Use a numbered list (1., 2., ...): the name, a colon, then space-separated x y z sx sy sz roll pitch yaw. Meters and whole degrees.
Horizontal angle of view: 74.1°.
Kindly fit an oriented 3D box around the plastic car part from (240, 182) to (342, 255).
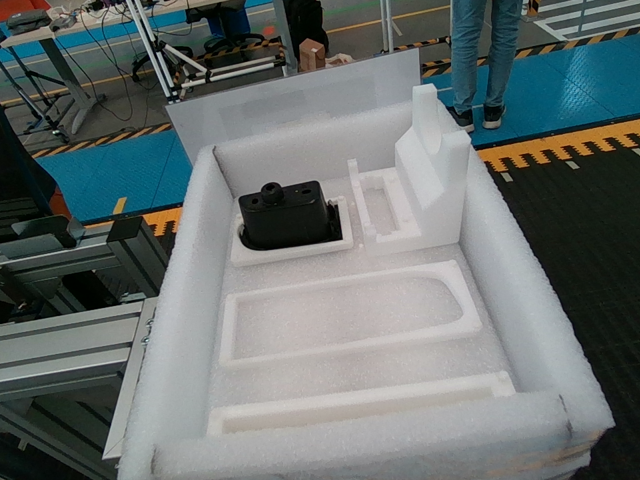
1. plastic car part: -0.038 -0.029 0.463 0.117 0.071 0.066 -7 42 4
